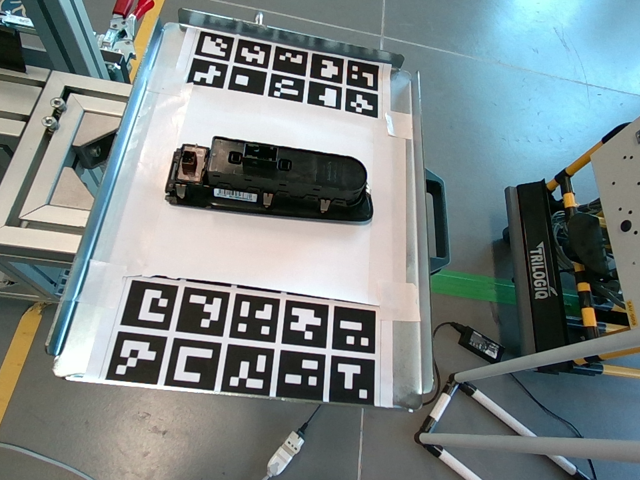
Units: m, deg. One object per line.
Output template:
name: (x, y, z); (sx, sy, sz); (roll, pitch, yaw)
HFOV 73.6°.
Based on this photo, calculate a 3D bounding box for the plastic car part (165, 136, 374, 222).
plastic car part: (-0.041, -0.063, 0.410); (0.203, 0.066, 0.067); (9, -32, -11)
